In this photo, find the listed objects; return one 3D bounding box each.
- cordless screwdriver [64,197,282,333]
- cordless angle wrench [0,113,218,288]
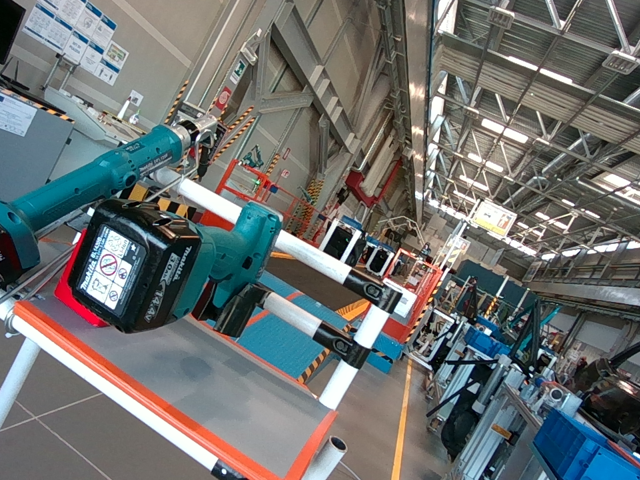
[{"bbox_3d":[-0.129,0.036,0.436,0.074,0.159,0.248,26,11,15],"label":"cordless screwdriver"},{"bbox_3d":[-0.293,-0.096,0.606,0.074,0.098,0.421,32,48,13],"label":"cordless angle wrench"}]
